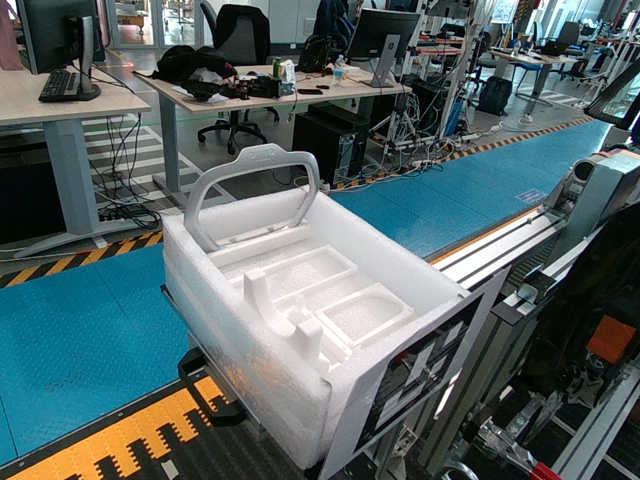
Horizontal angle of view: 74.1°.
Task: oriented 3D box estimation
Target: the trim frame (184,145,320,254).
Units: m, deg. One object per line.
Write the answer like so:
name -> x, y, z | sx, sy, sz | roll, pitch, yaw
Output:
trim frame -> -0.101, -0.064, 0.690 | 0.247, 0.184, 0.027 | -17, 46, -31
